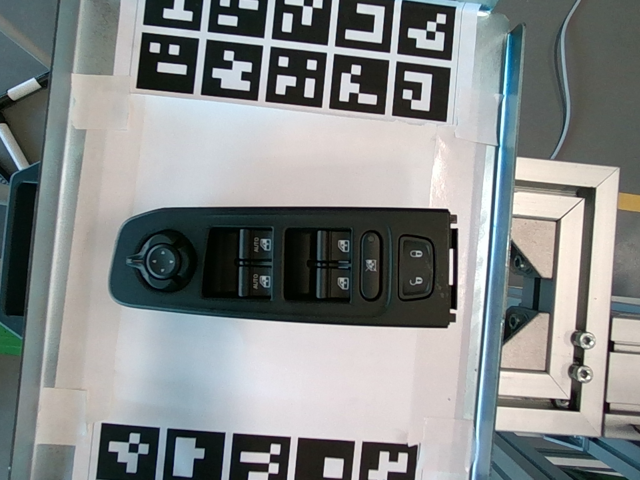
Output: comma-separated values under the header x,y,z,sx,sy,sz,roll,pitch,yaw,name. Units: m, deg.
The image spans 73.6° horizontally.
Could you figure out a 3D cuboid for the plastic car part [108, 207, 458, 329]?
x,y,z,sx,sy,sz,roll,pitch,yaw,name
-0.025,0.013,0.265,0.203,0.066,0.067,1,3,3,plastic car part
